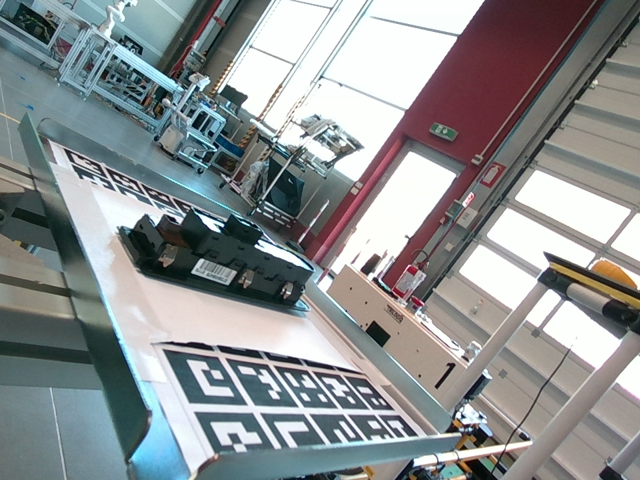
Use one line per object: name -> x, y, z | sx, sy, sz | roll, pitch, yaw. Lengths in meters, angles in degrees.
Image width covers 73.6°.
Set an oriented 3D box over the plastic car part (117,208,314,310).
plastic car part -> -0.073, 0.017, 0.392 | 0.066, 0.067, 0.202 | 32, 1, 40
